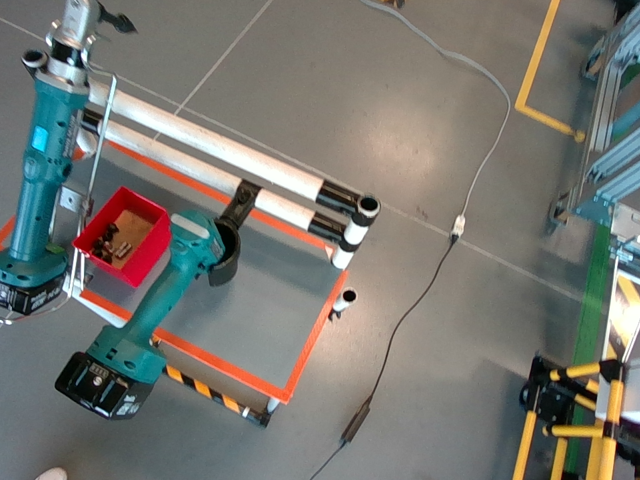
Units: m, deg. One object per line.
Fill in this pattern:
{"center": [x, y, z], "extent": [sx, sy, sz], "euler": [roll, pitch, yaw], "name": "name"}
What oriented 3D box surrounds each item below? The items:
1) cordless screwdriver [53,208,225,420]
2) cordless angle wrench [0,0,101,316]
{"center": [-0.198, 0.088, 0.529], "extent": [0.074, 0.248, 0.159], "euler": [27, -16, 5], "name": "cordless screwdriver"}
{"center": [-0.354, -0.102, 0.554], "extent": [0.074, 0.423, 0.098], "euler": [24, 17, 0], "name": "cordless angle wrench"}
